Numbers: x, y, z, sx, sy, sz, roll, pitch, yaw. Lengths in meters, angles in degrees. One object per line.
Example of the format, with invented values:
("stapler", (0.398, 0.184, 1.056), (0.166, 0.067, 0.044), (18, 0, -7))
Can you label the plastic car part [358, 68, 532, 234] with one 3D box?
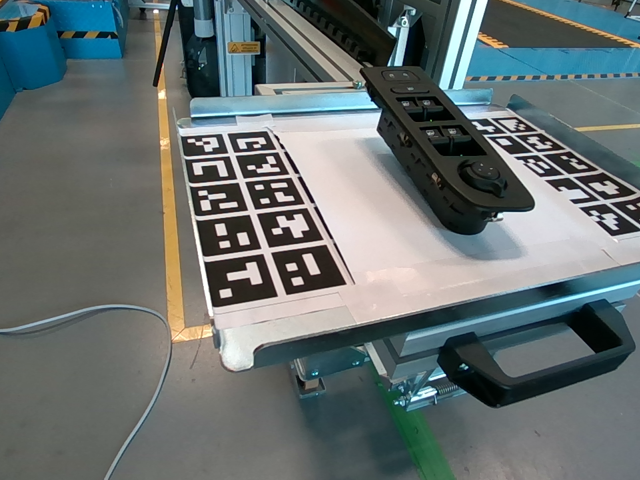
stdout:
("plastic car part", (0.092, -0.079, 0.365), (0.066, 0.067, 0.203), (-4, 44, -24))
